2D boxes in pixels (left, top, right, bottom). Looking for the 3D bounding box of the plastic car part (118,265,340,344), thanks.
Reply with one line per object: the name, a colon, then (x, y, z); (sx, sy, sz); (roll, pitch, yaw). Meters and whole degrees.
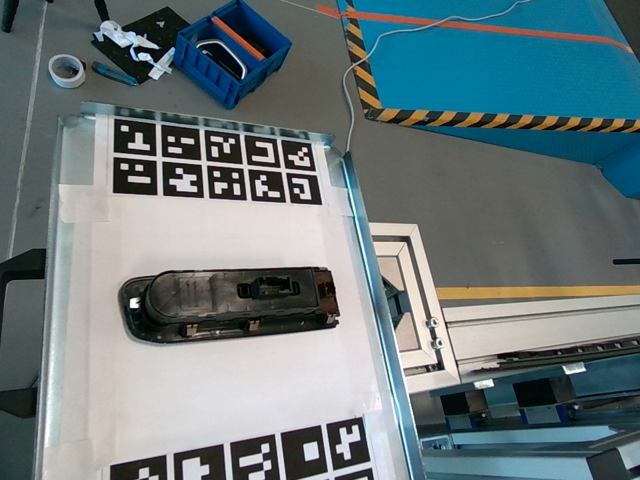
plastic car part: (-0.068, 0.053, 0.380); (0.202, 0.066, 0.067); (-1, -17, -24)
